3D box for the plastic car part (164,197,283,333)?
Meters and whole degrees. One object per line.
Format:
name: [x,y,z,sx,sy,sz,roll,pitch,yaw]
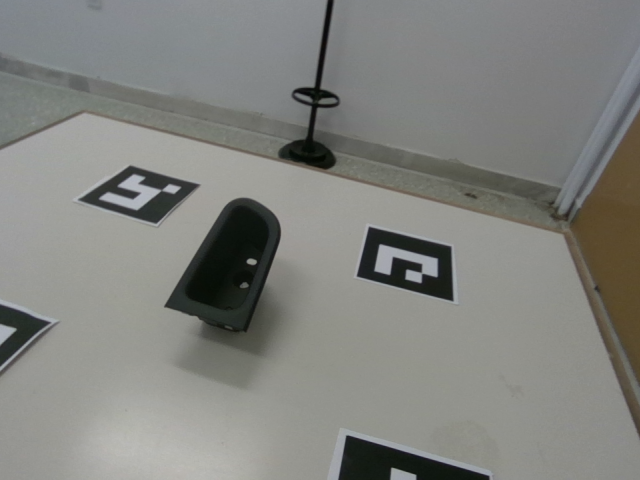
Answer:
plastic car part: [-0.069,0.030,0.360,0.066,0.116,0.071,16,-38,5]
